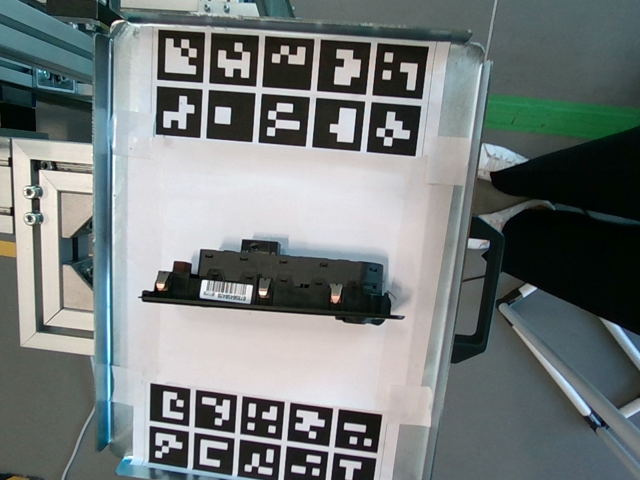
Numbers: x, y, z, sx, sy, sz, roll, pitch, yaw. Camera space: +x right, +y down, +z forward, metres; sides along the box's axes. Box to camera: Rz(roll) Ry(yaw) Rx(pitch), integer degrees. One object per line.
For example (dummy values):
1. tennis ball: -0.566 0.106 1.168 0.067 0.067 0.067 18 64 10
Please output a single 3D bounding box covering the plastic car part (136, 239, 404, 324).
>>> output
1. plastic car part: -0.034 0.036 0.350 0.203 0.067 0.066 8 -16 4
